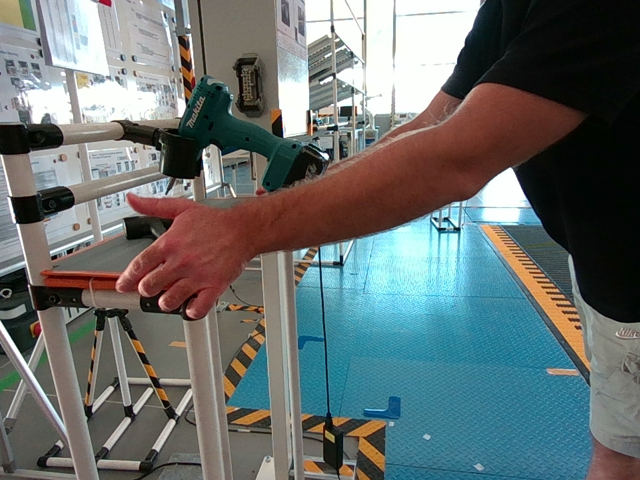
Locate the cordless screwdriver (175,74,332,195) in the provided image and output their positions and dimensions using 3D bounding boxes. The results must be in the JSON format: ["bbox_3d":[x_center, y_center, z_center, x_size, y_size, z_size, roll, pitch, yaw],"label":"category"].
[{"bbox_3d":[-0.116,-0.135,0.691,0.249,0.159,0.074,32,24,0],"label":"cordless screwdriver"}]
